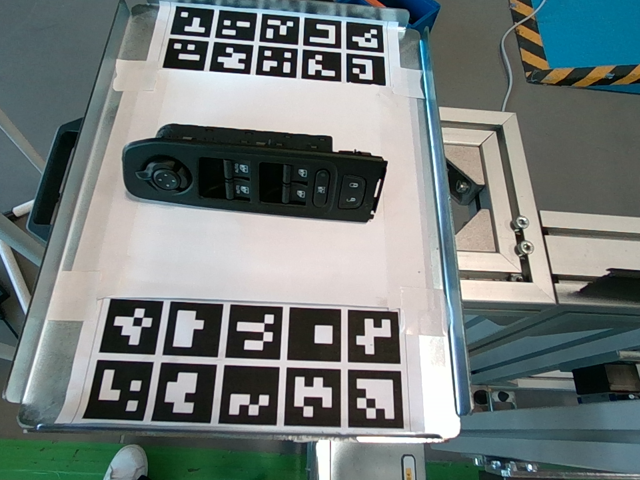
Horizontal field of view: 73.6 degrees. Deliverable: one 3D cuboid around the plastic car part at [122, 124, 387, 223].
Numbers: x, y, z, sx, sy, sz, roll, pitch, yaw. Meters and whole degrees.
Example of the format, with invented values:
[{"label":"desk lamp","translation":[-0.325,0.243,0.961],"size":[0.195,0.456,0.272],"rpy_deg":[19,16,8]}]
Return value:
[{"label":"plastic car part","translation":[-0.054,-0.061,0.344],"size":[0.203,0.067,0.066],"rpy_deg":[1,-36,-4]}]
